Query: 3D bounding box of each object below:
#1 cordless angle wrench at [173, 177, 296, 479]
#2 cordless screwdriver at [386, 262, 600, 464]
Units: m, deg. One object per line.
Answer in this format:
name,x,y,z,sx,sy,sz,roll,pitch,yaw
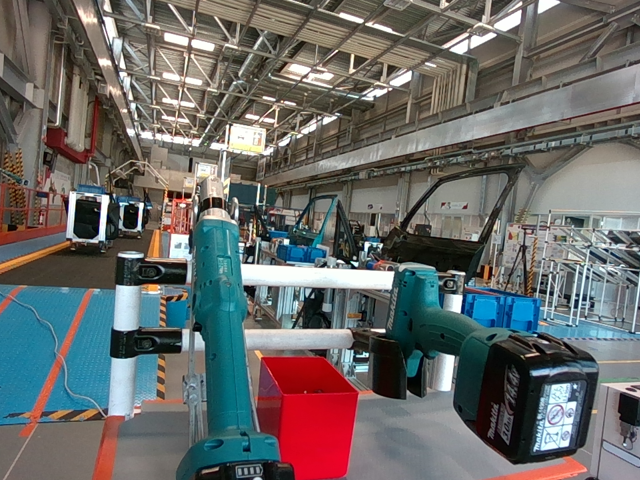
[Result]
cordless angle wrench,-0.105,0.070,0.438,0.074,0.421,0.098,11,-49,-27
cordless screwdriver,0.140,0.130,0.436,0.074,0.159,0.248,3,12,-19
